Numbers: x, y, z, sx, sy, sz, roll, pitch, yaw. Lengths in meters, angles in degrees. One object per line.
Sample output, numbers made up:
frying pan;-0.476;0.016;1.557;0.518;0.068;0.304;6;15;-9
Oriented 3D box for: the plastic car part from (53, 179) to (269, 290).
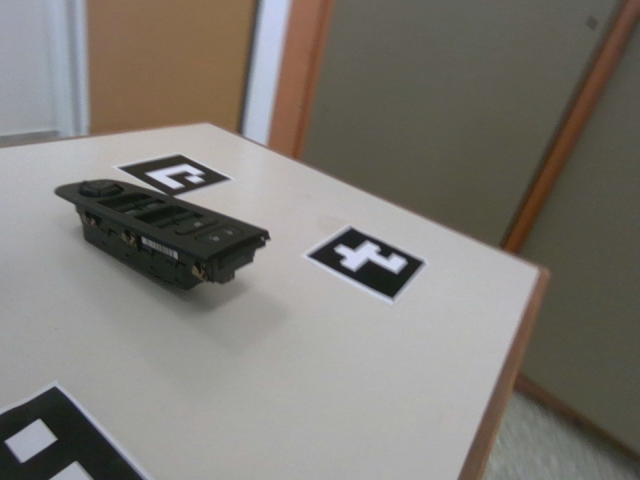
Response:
plastic car part;-0.139;-0.007;0.357;0.204;0.067;0.066;23;39;26
